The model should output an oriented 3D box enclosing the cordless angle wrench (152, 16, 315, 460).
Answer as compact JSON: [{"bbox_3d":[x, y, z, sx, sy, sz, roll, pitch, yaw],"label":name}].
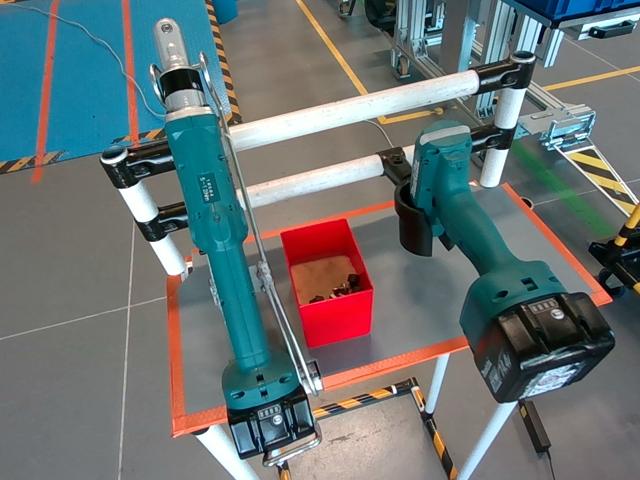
[{"bbox_3d":[-0.099,-0.012,0.416,0.074,0.423,0.098,-15,0,-12],"label":"cordless angle wrench"}]

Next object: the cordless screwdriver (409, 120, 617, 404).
[{"bbox_3d":[0.148,0.022,0.403,0.074,0.248,0.159,-14,-35,-4],"label":"cordless screwdriver"}]
